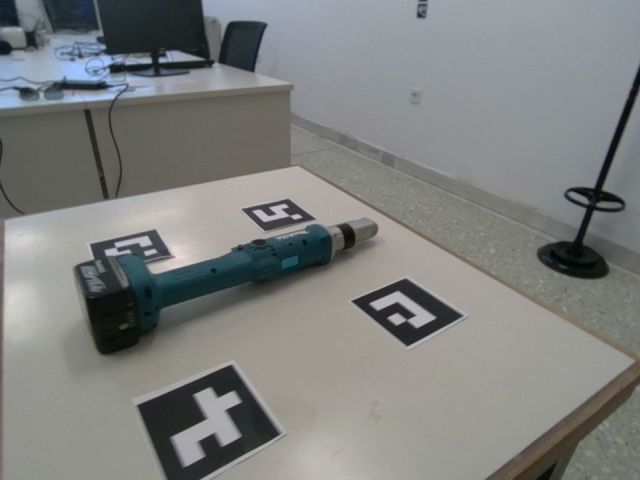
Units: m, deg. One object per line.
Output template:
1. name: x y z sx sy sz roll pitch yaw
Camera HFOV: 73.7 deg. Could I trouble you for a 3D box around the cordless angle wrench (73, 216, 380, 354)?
1. cordless angle wrench: -0.084 0.027 0.572 0.419 0.074 0.099 -16 34 -30
